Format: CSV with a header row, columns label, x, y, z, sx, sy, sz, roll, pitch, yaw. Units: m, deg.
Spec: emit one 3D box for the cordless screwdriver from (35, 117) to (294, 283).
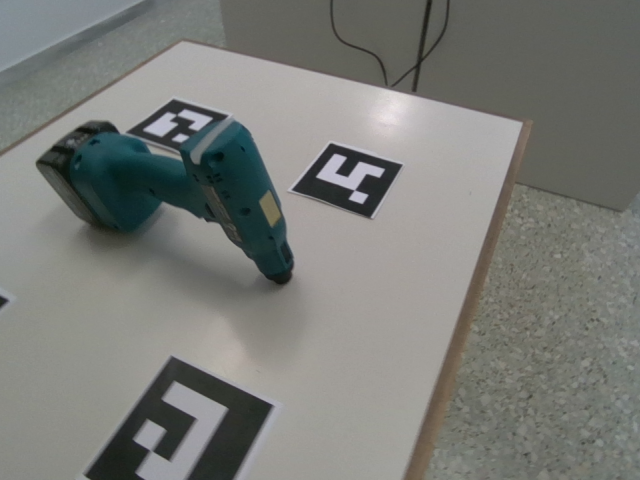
label,x,y,z,sx,sy,sz,roll,pitch,yaw
cordless screwdriver,-0.140,-0.036,0.406,0.251,0.074,0.158,10,-40,31
